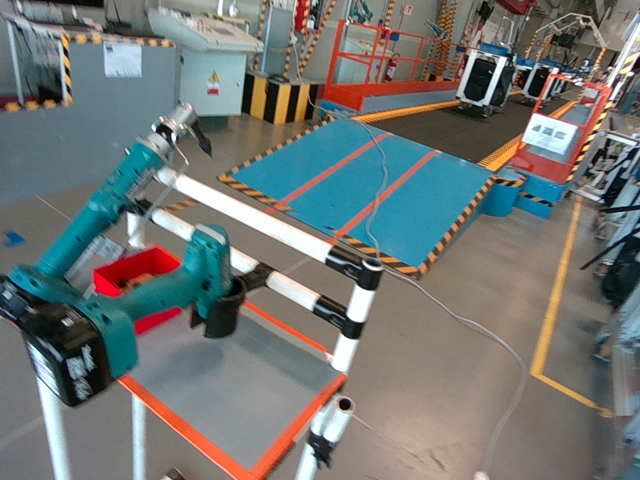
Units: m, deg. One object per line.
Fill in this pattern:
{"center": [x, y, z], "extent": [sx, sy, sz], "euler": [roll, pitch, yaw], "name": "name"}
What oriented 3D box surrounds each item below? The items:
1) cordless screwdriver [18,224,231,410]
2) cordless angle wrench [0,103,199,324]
{"center": [-0.204, 0.095, 0.510], "extent": [0.074, 0.160, 0.248], "euler": [27, 39, 24], "name": "cordless screwdriver"}
{"center": [-0.329, -0.058, 0.668], "extent": [0.074, 0.422, 0.098], "euler": [28, -15, 18], "name": "cordless angle wrench"}
